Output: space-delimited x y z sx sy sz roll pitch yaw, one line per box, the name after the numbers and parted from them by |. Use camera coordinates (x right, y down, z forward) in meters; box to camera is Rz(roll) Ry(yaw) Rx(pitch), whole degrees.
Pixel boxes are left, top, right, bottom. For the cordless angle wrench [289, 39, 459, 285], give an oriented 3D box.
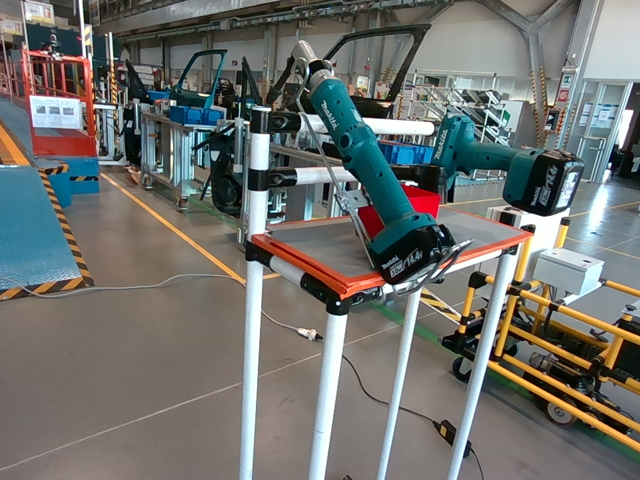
0.052 -0.140 0.622 0.074 0.422 0.098 -7 -26 -44 | cordless angle wrench

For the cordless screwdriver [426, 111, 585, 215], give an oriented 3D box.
0.290 -0.110 0.718 0.074 0.159 0.249 -11 34 -38 | cordless screwdriver
